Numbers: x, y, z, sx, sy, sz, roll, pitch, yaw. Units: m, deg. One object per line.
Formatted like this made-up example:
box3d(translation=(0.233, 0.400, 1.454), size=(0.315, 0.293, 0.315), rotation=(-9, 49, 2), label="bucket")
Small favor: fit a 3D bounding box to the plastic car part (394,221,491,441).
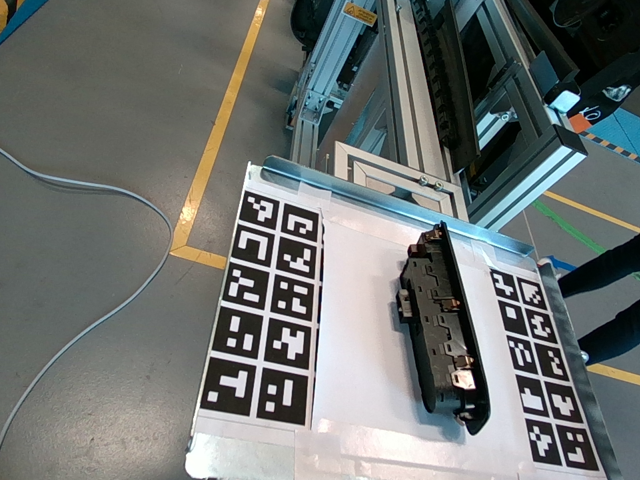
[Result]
box3d(translation=(0.109, 0.077, 0.401), size=(0.067, 0.202, 0.066), rotation=(1, -38, -11), label="plastic car part")
